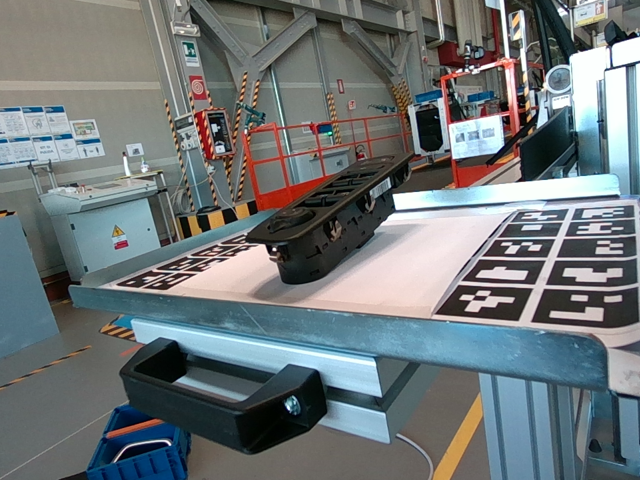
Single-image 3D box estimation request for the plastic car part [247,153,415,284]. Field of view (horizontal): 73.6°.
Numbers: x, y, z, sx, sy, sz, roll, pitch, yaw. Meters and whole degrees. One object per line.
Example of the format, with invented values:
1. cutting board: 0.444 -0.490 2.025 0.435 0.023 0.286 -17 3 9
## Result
1. plastic car part: 0.016 -0.022 0.366 0.067 0.067 0.201 7 25 33
